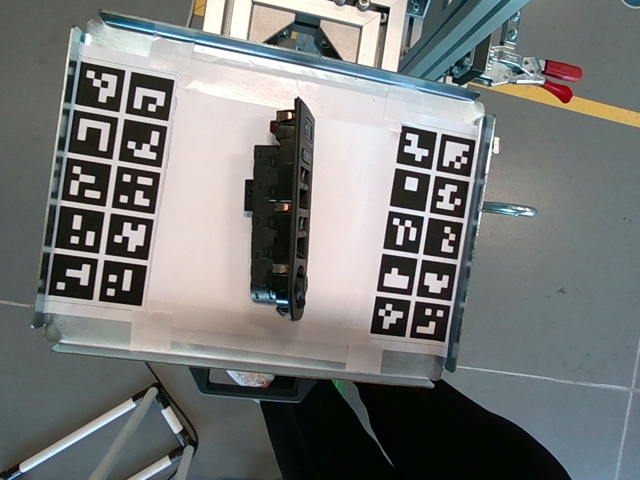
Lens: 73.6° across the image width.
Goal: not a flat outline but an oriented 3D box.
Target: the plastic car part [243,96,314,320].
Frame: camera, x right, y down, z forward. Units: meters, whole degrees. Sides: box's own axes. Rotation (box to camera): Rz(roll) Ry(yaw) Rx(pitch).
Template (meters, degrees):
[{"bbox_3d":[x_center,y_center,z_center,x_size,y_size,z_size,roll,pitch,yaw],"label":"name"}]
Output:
[{"bbox_3d":[-0.038,-0.023,0.398,0.067,0.203,0.066,-1,3,1],"label":"plastic car part"}]
